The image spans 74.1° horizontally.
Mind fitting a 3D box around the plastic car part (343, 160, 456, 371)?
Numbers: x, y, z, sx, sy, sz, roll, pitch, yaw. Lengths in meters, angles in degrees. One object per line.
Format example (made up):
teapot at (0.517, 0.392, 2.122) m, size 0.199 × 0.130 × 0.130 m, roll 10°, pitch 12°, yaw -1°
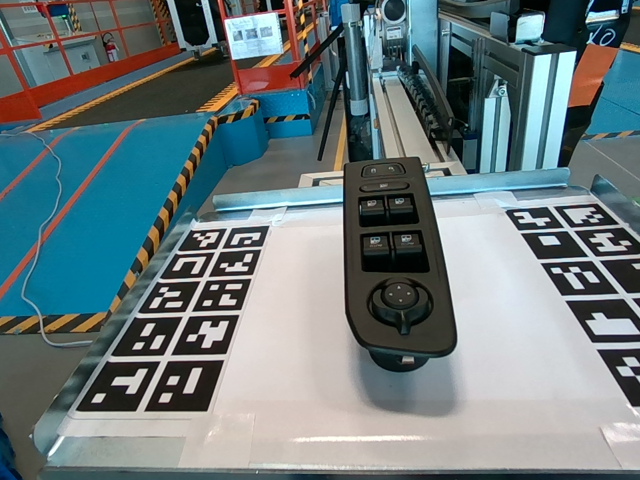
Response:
plastic car part at (0.049, 0.012, 0.311) m, size 0.066 × 0.067 × 0.202 m, roll 2°, pitch 36°, yaw 2°
